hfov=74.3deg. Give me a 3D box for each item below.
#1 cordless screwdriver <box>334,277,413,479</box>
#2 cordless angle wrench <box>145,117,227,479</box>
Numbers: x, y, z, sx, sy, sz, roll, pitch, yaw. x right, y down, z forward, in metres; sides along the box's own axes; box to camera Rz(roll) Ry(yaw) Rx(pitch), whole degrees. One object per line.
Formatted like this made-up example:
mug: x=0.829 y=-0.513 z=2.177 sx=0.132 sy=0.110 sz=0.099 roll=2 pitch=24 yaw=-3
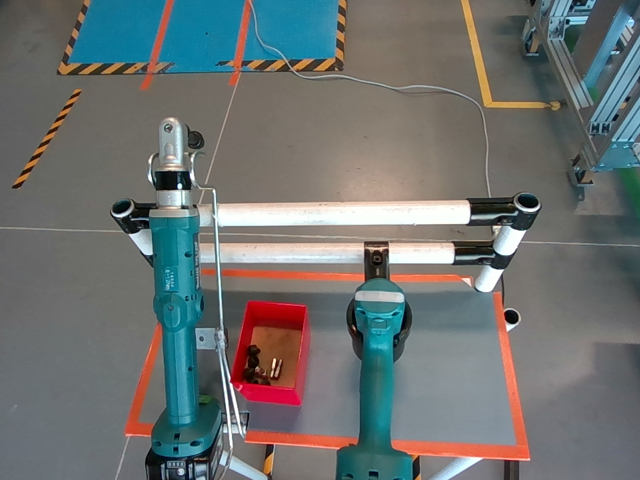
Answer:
cordless screwdriver: x=0.060 y=0.178 z=0.445 sx=0.074 sy=0.248 sz=0.159 roll=1 pitch=-25 yaw=10
cordless angle wrench: x=-0.162 y=0.074 z=0.494 sx=0.074 sy=0.423 sz=0.098 roll=-1 pitch=7 yaw=2
